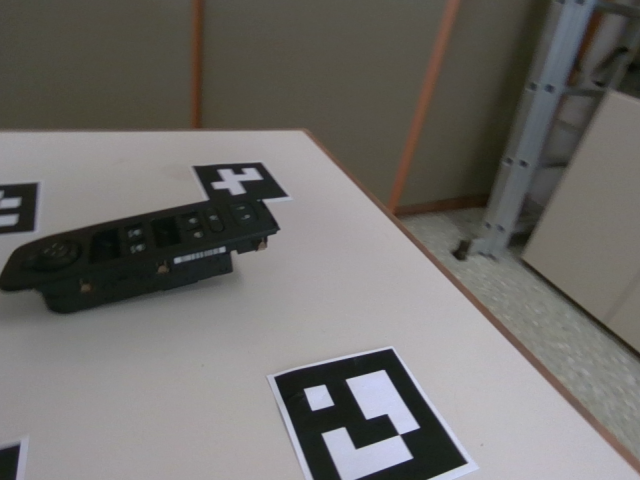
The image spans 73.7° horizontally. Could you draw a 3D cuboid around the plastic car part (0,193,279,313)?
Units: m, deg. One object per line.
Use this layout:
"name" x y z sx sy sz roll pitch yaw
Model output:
"plastic car part" -0.141 0.012 0.350 0.201 0.067 0.067 -11 48 -23
